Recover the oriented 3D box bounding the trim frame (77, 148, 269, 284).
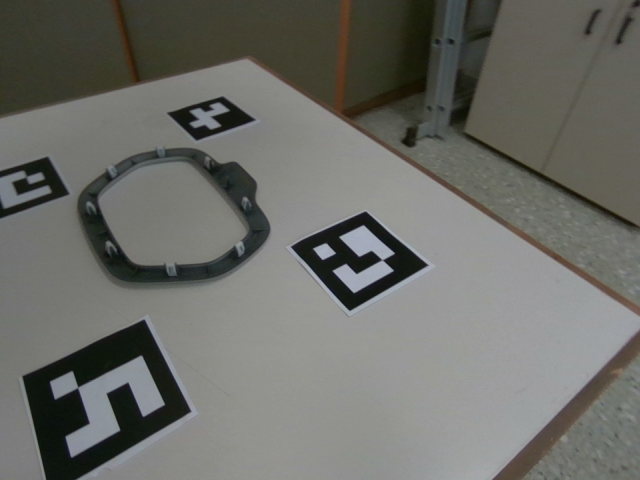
[{"bbox_3d":[-0.164,-0.040,0.476,0.182,0.027,0.250,-24,47,-26],"label":"trim frame"}]
